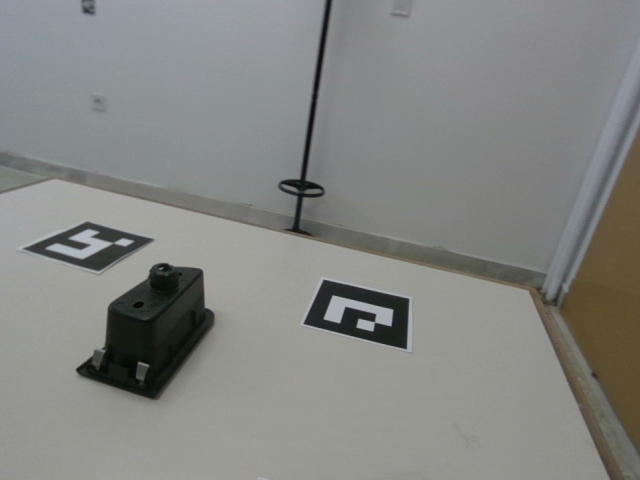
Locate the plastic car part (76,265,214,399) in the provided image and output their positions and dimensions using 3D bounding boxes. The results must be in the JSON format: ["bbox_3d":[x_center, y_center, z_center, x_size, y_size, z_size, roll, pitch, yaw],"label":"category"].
[{"bbox_3d":[-0.132,0.059,0.350,0.066,0.071,0.116,14,27,8],"label":"plastic car part"}]
